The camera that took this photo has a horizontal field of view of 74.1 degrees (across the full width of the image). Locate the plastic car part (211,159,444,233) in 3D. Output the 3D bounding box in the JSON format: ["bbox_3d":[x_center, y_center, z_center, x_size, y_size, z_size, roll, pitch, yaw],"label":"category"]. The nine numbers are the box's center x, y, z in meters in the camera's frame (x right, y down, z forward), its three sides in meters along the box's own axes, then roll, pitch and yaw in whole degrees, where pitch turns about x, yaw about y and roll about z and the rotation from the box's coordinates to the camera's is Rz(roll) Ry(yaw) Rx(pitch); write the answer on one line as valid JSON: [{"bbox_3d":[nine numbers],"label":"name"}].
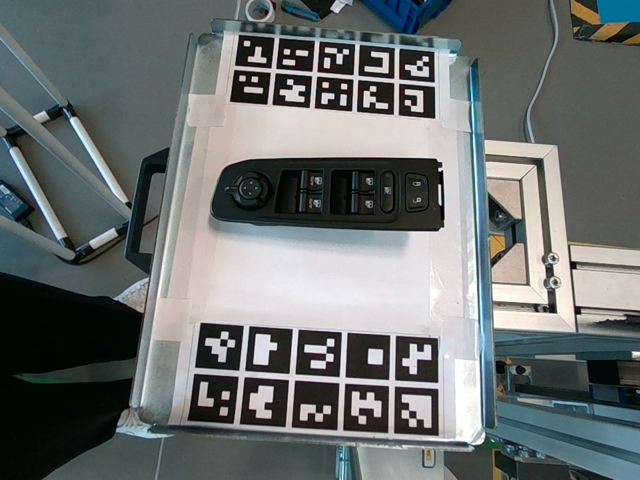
[{"bbox_3d":[0.005,-0.039,0.392,0.203,0.066,0.067,2,-8,2],"label":"plastic car part"}]
